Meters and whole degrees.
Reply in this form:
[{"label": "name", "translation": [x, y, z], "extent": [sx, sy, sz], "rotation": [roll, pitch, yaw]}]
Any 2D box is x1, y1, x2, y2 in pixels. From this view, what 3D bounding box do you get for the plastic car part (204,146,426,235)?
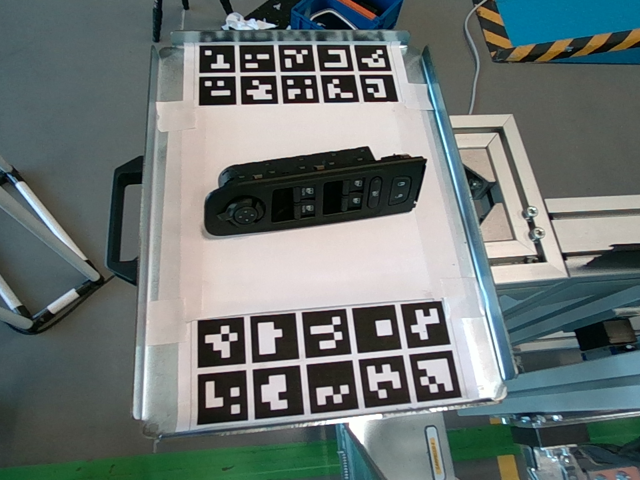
[{"label": "plastic car part", "translation": [-0.009, -0.052, 0.397], "extent": [0.202, 0.067, 0.066], "rotation": [-13, -33, -10]}]
